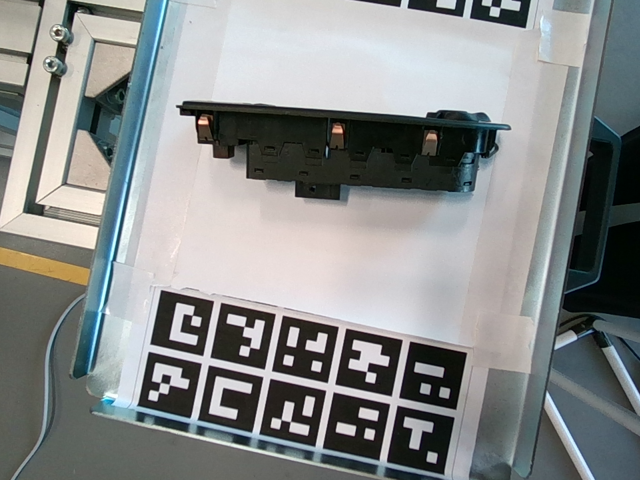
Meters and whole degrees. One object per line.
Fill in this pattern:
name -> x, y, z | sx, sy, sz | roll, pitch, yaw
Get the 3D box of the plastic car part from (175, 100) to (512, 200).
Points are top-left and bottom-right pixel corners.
plastic car part -> 0.018, -0.059, 0.274 | 0.203, 0.067, 0.066 | 1, 11, 5
